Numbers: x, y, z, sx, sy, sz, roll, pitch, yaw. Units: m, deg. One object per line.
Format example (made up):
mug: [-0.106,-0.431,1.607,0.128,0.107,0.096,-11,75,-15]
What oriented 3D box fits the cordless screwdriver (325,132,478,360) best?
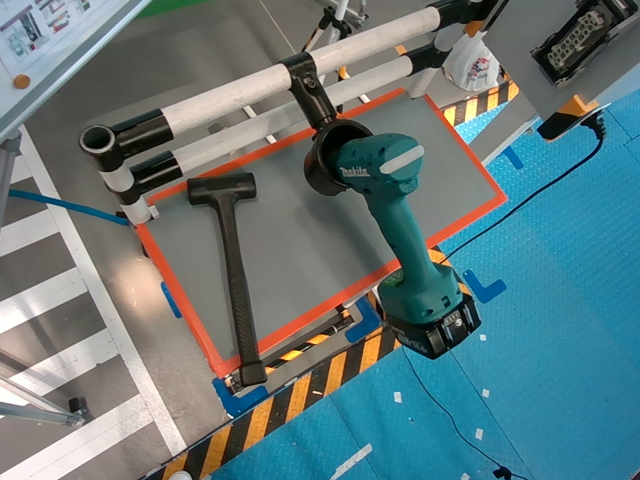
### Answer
cordless screwdriver: [0.077,0.002,0.485,0.074,0.248,0.160,-29,18,-19]
